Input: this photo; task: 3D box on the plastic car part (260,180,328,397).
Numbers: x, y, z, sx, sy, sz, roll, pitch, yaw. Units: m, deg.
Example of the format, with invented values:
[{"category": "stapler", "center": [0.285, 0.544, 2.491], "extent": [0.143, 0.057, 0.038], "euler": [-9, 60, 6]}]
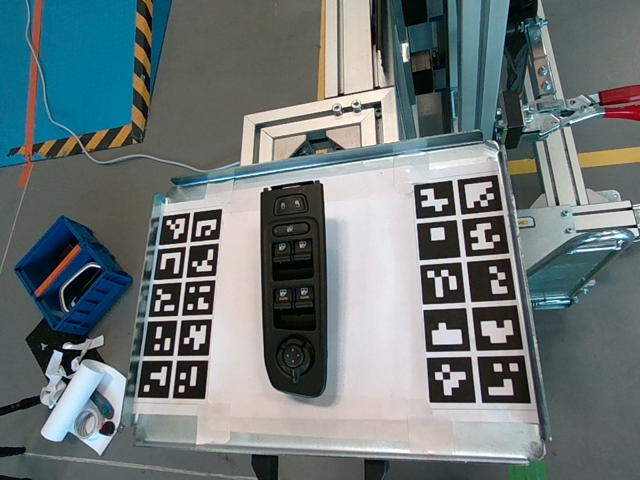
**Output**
[{"category": "plastic car part", "center": [-0.022, 0.047, 0.424], "extent": [0.066, 0.202, 0.067], "euler": [-4, -17, 8]}]
